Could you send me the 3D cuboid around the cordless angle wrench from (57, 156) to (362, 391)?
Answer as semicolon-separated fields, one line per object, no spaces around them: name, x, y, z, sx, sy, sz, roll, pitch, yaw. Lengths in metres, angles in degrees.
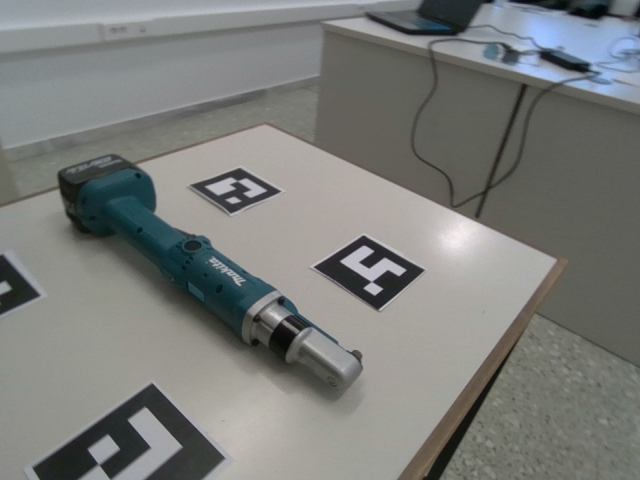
cordless angle wrench;-0.136;0.026;0.462;0.426;0.074;0.097;30;41;27
